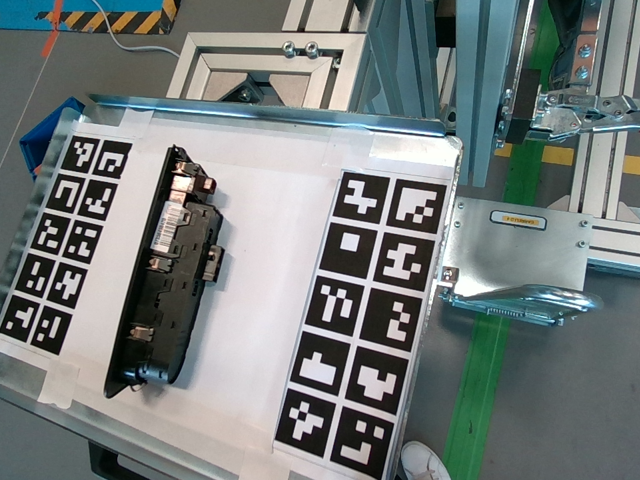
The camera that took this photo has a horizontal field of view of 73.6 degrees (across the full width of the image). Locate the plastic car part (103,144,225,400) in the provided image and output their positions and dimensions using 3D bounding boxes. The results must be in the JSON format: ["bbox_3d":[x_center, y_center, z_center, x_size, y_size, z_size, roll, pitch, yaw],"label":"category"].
[{"bbox_3d":[-0.121,0.031,0.356,0.067,0.202,0.066,18,-9,-6],"label":"plastic car part"}]
